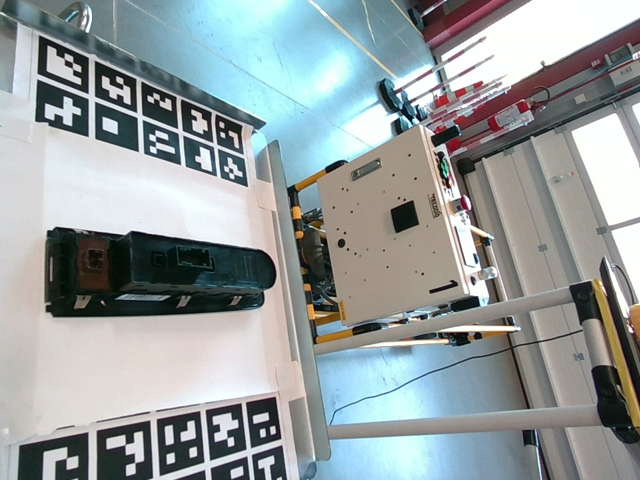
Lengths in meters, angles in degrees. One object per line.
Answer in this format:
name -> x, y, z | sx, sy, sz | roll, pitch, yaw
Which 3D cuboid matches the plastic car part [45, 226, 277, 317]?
plastic car part -> -0.111, 0.024, 0.364 | 0.067, 0.066, 0.202 | -28, -23, 29
